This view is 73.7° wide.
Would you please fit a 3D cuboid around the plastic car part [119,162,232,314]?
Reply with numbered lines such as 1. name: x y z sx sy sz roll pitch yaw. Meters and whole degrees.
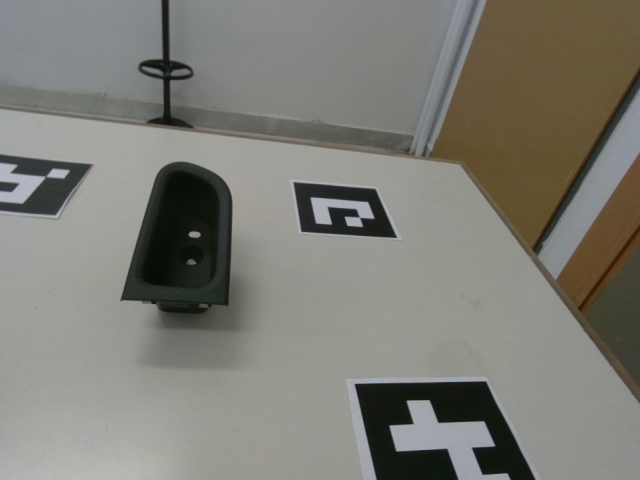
1. plastic car part: -0.099 0.008 0.319 0.066 0.116 0.071 5 -37 -11
